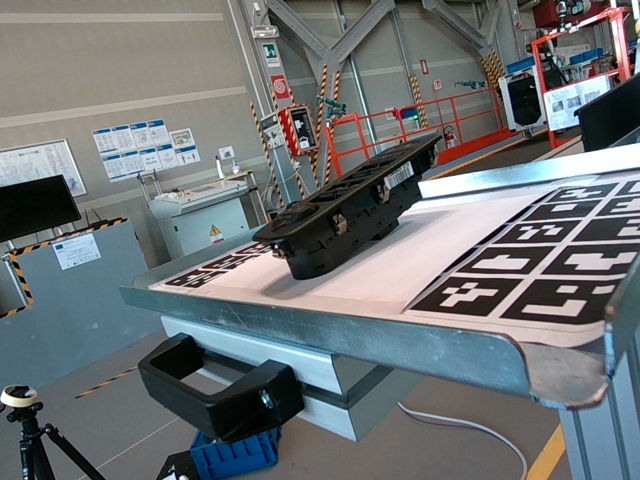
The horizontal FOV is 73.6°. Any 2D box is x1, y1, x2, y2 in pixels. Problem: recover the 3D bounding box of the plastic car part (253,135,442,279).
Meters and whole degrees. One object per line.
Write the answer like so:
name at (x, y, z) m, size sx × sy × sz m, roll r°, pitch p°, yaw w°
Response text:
plastic car part at (0.030, -0.028, 0.358) m, size 0.067 × 0.067 × 0.201 m, roll 6°, pitch 28°, yaw 45°
